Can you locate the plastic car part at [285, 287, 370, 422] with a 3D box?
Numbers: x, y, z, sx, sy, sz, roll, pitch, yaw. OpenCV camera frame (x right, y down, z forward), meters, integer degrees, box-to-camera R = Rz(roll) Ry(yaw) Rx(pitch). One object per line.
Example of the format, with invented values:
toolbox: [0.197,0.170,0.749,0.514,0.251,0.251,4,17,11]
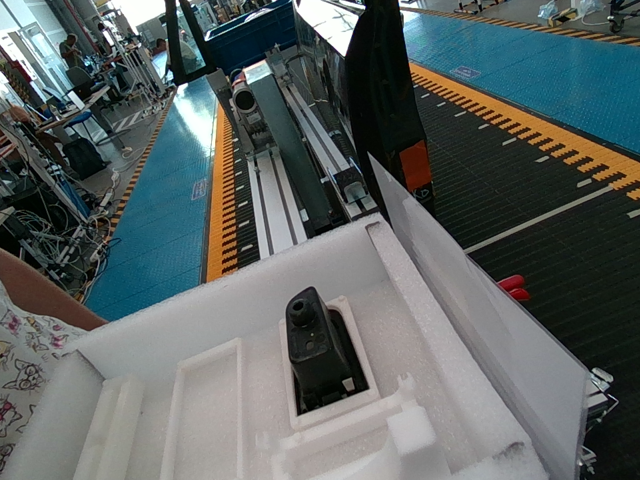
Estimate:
plastic car part: [-0.007,0.090,0.389,0.066,0.071,0.116,-21,36,3]
